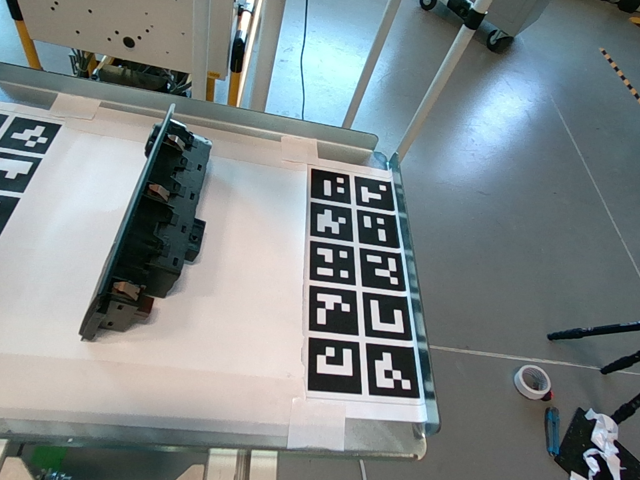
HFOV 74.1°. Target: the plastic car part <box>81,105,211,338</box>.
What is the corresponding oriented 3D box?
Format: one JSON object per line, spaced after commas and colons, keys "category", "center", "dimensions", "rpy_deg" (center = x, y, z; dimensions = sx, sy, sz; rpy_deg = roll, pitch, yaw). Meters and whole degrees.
{"category": "plastic car part", "center": [-0.120, -0.027, 0.324], "dimensions": [0.067, 0.202, 0.067], "rpy_deg": [12, -40, -21]}
